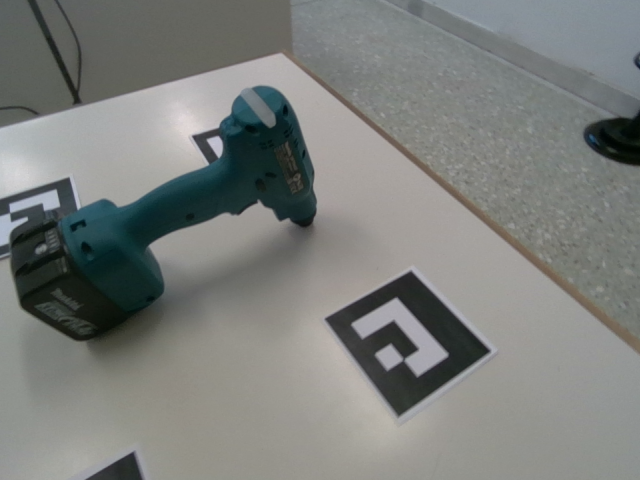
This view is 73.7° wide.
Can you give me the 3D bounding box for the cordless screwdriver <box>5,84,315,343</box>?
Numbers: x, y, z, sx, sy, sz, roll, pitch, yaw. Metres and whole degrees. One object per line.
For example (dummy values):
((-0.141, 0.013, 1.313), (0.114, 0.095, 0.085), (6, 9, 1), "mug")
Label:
((-0.115, -0.009, 0.373), (0.248, 0.075, 0.158), (-33, -33, -8), "cordless screwdriver")
